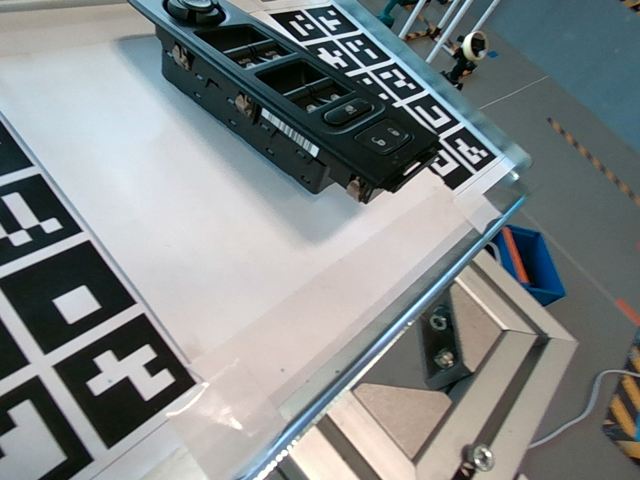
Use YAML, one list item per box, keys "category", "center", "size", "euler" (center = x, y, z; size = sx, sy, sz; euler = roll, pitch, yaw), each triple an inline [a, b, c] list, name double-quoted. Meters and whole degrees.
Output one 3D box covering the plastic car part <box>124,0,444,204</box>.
- category: "plastic car part"
  center: [-0.031, -0.087, 0.255]
  size: [0.066, 0.203, 0.067]
  euler: [-41, -15, -32]
